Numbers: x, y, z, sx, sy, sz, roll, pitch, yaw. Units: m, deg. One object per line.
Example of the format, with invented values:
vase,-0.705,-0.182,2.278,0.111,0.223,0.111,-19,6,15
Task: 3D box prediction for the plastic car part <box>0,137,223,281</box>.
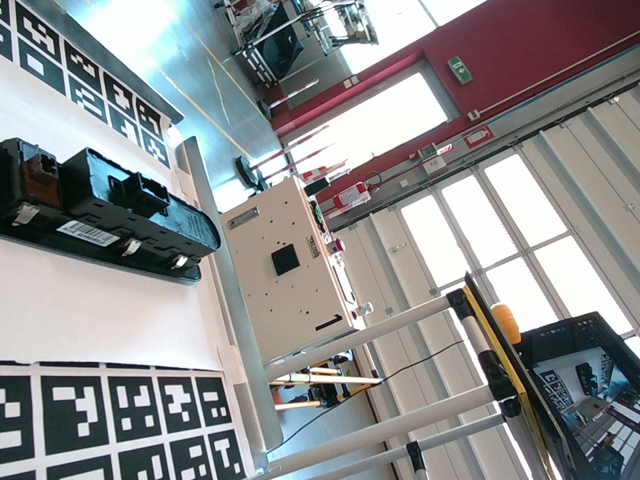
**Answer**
plastic car part,-0.140,-0.018,0.327,0.067,0.066,0.202,-31,-24,7
